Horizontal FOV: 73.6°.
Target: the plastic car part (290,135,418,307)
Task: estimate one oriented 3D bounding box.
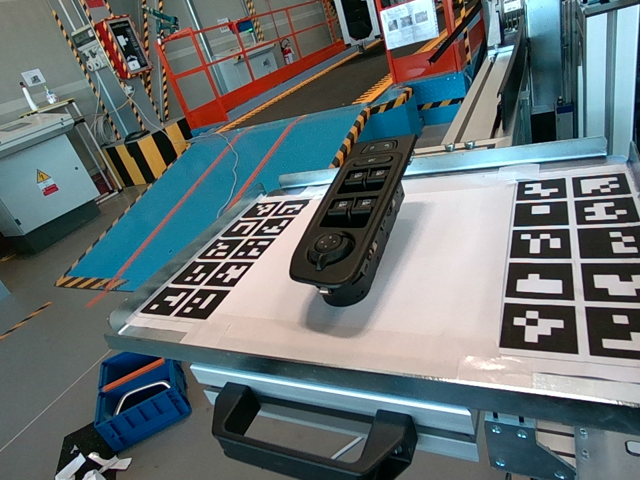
[{"bbox_3d":[0.034,-0.019,0.370,0.067,0.067,0.202,5,38,24],"label":"plastic car part"}]
